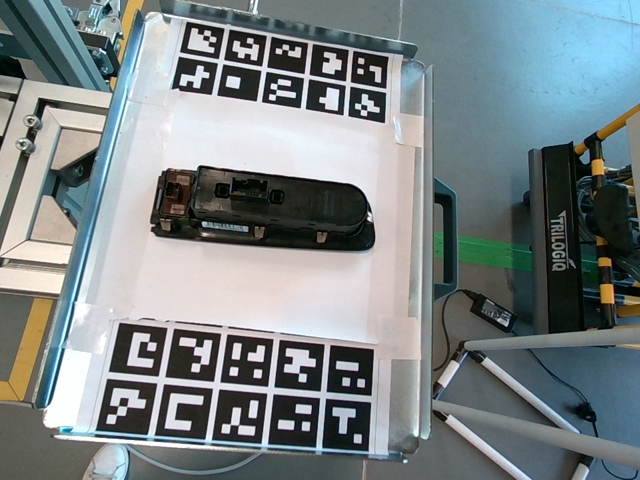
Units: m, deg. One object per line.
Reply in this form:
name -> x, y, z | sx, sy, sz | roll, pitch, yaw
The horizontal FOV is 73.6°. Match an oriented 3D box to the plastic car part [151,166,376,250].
plastic car part -> -0.043, -0.033, 0.377 | 0.203, 0.066, 0.067 | 7, -23, -9
